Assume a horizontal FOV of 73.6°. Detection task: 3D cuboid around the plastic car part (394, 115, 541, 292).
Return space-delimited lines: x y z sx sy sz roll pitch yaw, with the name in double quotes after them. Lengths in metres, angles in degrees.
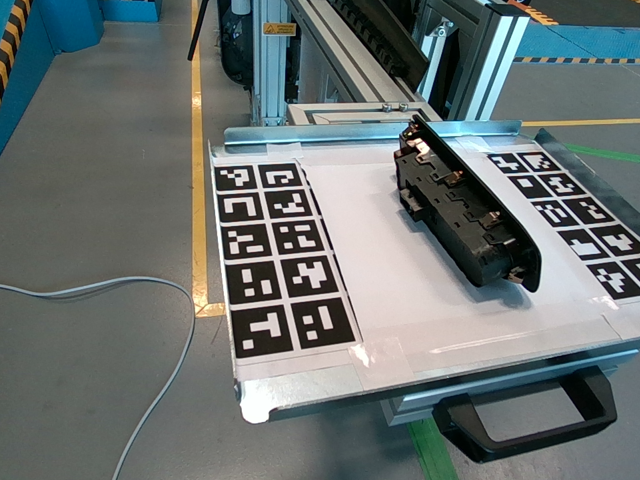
0.119 -0.033 0.391 0.067 0.203 0.066 -22 -40 -12 "plastic car part"
